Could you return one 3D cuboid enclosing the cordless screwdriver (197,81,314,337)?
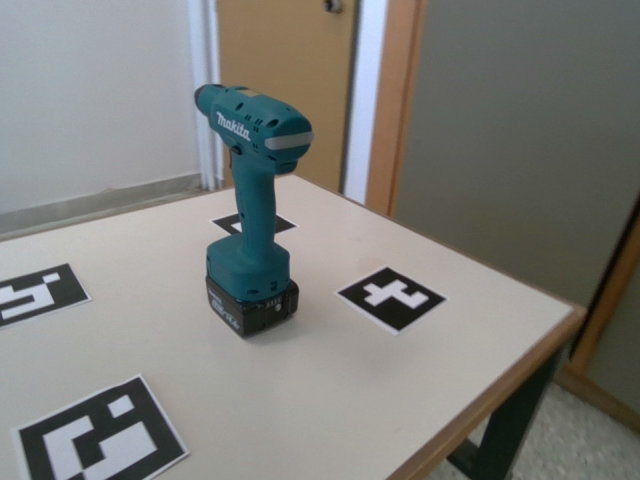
[{"bbox_3d":[-0.083,-0.033,0.450,0.073,0.249,0.160,-18,40,-35],"label":"cordless screwdriver"}]
